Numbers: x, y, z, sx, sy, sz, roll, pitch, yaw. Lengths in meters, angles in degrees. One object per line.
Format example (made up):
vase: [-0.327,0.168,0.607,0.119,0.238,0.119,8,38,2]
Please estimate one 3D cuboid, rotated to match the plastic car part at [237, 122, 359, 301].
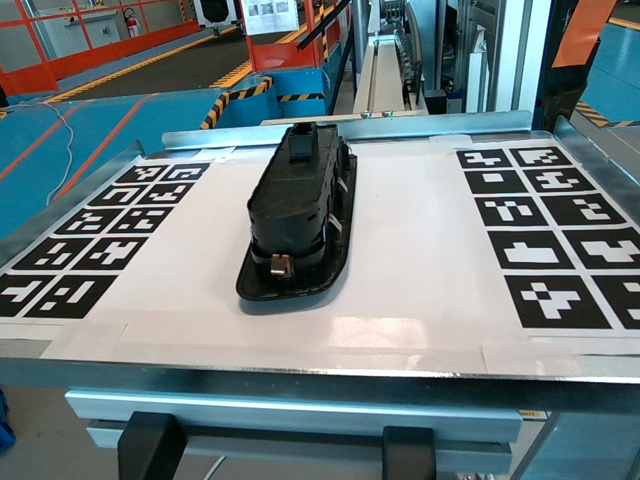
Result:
plastic car part: [-0.008,-0.038,0.292,0.066,0.067,0.202,3,36,5]
